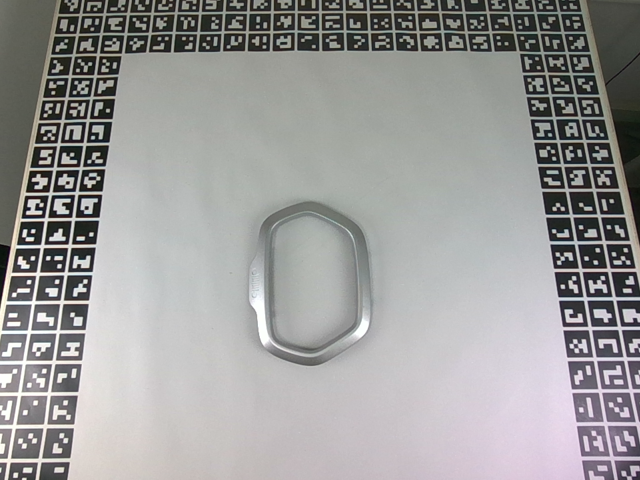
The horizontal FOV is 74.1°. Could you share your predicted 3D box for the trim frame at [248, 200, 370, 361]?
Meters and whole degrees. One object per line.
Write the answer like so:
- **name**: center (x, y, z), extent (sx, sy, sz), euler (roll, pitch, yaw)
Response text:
- **trim frame**: center (-0.017, 0.064, 0.641), extent (0.184, 0.248, 0.027), euler (-2, 8, -1)
